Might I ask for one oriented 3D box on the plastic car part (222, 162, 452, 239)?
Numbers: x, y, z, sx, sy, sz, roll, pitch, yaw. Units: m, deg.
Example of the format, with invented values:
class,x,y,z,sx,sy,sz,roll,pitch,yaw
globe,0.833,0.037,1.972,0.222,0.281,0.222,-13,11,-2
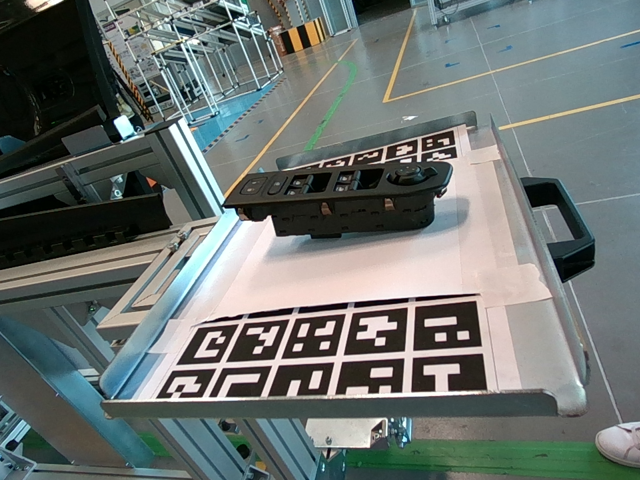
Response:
class,x,y,z,sx,sy,sz,roll,pitch,yaw
plastic car part,0.017,-0.034,0.394,0.204,0.067,0.066,-6,24,19
